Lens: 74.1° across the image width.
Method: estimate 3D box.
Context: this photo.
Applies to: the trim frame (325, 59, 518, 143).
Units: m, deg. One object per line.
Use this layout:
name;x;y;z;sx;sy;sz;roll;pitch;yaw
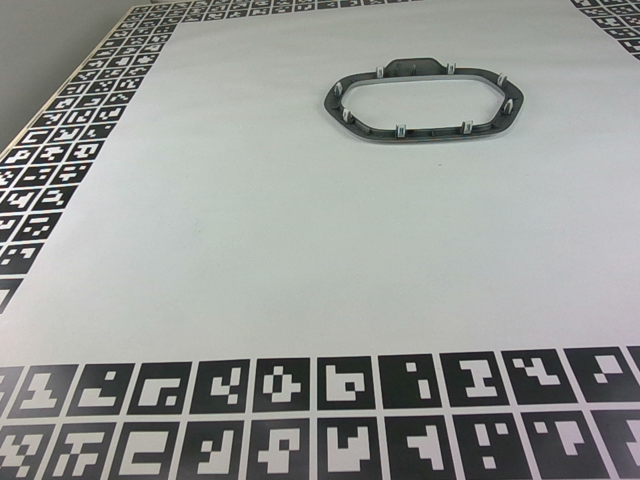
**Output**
trim frame;0.130;-0.185;0.552;0.249;0.183;0.027;-3;-43;4
